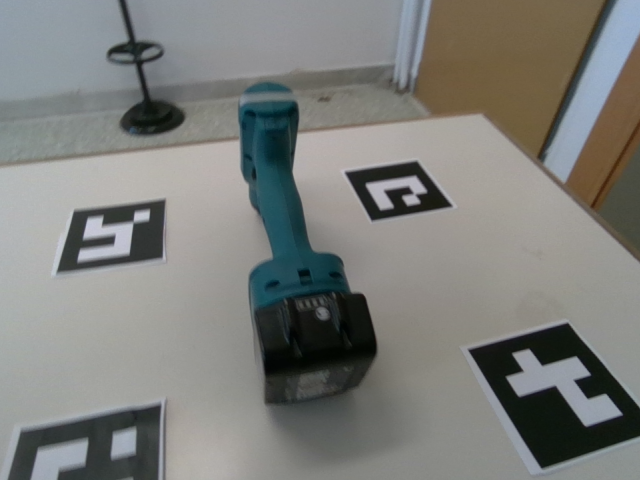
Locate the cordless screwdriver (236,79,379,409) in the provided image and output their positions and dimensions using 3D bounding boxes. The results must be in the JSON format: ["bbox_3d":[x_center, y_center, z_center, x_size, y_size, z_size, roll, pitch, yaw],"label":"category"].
[{"bbox_3d":[-0.031,0.007,0.359,0.074,0.249,0.159,-6,-31,-13],"label":"cordless screwdriver"}]
